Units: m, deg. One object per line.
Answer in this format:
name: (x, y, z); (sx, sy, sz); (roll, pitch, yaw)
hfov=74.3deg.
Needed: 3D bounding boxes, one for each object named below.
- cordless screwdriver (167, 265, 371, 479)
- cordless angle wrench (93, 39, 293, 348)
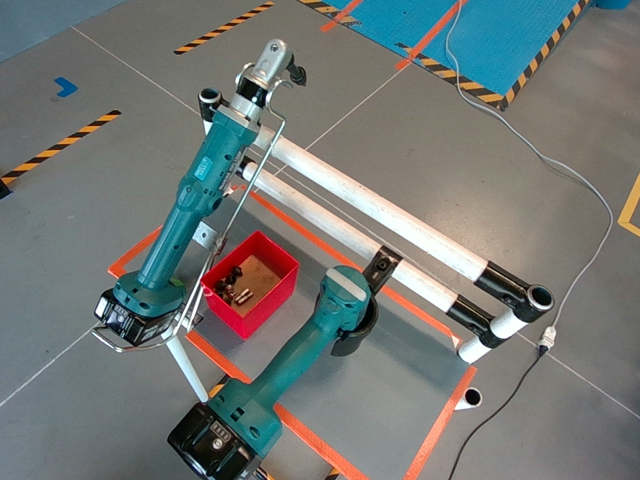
cordless screwdriver: (-0.037, 0.148, 0.466); (0.074, 0.248, 0.159); (37, -21, 17)
cordless angle wrench: (-0.151, -0.058, 0.541); (0.074, 0.423, 0.098); (33, 10, 11)
